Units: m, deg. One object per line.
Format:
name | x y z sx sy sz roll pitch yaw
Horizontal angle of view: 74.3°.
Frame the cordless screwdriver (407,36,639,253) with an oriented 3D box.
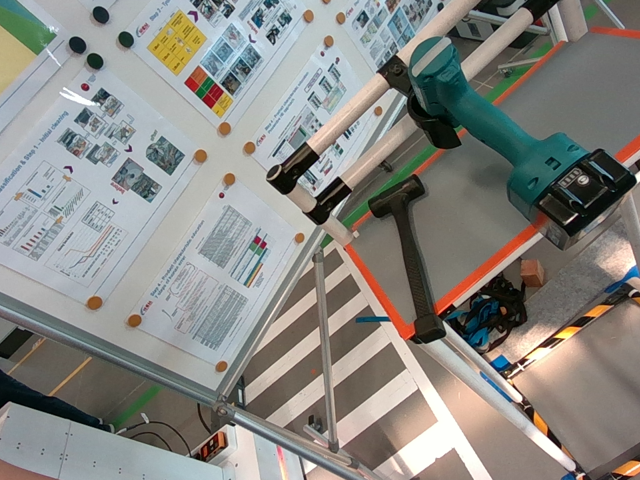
cordless screwdriver | 0.197 -0.100 0.458 0.074 0.248 0.159 -42 -23 9
